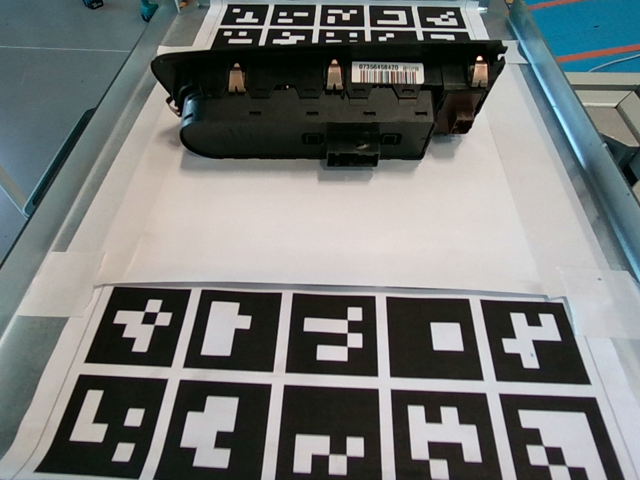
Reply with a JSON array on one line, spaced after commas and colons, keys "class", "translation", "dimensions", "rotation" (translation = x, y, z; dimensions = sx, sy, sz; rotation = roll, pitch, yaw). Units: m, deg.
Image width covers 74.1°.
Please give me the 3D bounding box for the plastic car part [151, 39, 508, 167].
[{"class": "plastic car part", "translation": [0.001, -0.077, 0.258], "dimensions": [0.203, 0.067, 0.066], "rotation": [4, -13, 3]}]
